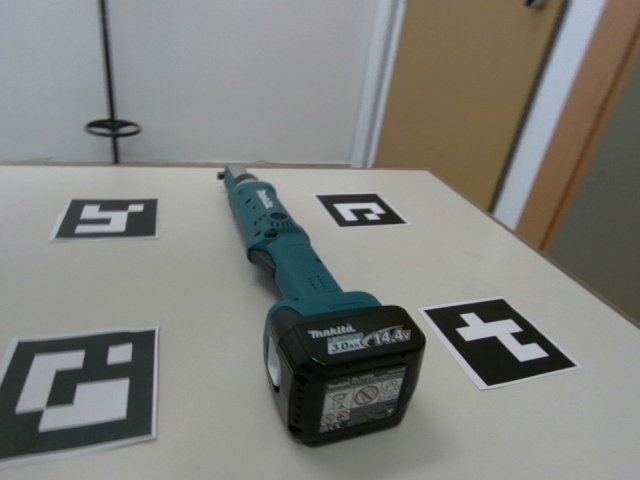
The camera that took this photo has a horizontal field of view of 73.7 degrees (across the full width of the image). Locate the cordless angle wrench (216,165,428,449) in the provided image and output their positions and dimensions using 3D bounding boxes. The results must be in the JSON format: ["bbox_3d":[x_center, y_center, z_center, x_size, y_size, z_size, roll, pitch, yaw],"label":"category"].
[{"bbox_3d":[-0.046,0.001,0.435,0.097,0.074,0.425,-3,29,-22],"label":"cordless angle wrench"}]
